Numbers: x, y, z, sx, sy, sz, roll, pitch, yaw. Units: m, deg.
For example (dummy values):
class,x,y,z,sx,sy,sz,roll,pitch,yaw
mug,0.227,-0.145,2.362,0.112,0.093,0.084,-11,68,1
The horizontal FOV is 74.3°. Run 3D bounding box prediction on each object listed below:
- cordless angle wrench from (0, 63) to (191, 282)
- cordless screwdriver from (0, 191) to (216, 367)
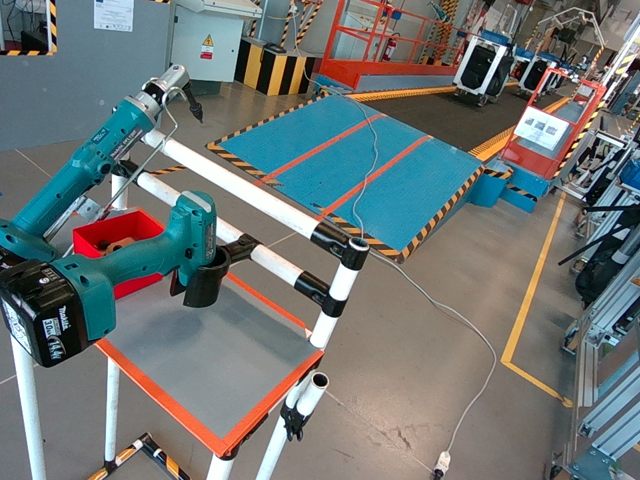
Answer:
class,x,y,z,sx,sy,sz,roll,pitch,yaw
cordless angle wrench,-0.342,-0.118,0.642,0.074,0.422,0.098,33,-14,15
cordless screwdriver,-0.226,0.051,0.509,0.074,0.160,0.248,30,42,23
